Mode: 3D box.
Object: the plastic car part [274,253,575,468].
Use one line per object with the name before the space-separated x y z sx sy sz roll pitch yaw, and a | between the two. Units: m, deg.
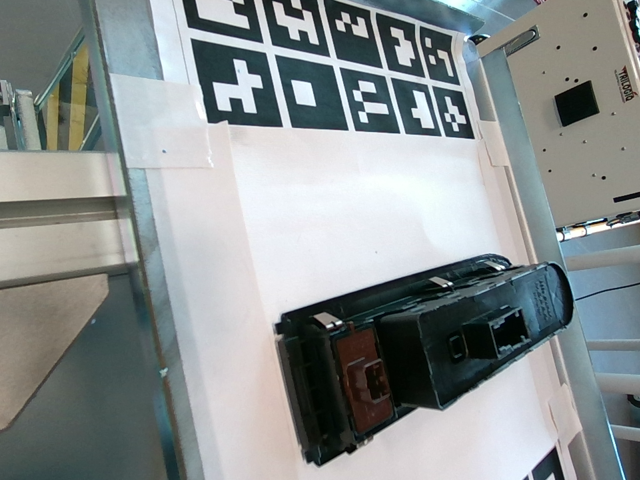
plastic car part | 0.077 0.043 0.225 0.201 0.066 0.067 -9 -13 -42
